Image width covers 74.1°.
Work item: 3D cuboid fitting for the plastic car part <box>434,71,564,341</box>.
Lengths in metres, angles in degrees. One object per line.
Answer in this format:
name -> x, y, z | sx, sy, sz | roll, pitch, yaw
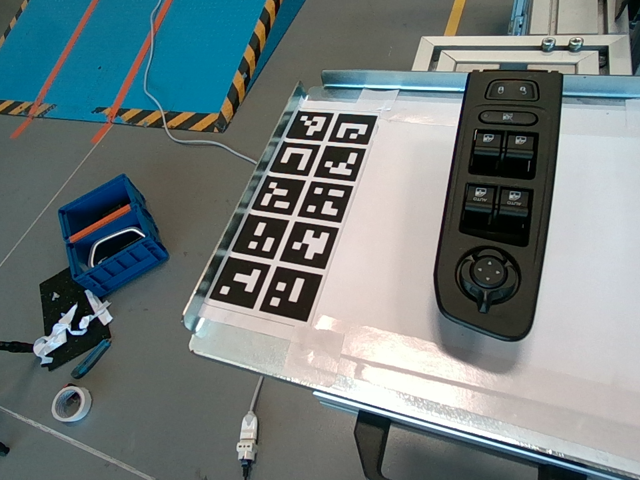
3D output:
plastic car part -> 0.122, -0.027, 0.299 | 0.066, 0.202, 0.067 | 12, -25, 12
